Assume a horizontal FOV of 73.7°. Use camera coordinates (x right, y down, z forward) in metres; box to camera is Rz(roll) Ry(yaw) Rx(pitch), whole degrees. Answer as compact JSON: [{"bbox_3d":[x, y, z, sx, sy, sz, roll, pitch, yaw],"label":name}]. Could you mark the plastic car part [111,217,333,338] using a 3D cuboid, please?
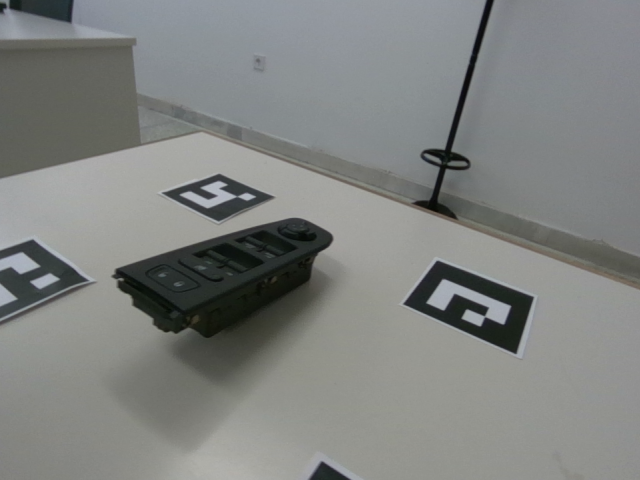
[{"bbox_3d":[-0.056,0.028,0.346,0.067,0.067,0.201,16,27,29],"label":"plastic car part"}]
